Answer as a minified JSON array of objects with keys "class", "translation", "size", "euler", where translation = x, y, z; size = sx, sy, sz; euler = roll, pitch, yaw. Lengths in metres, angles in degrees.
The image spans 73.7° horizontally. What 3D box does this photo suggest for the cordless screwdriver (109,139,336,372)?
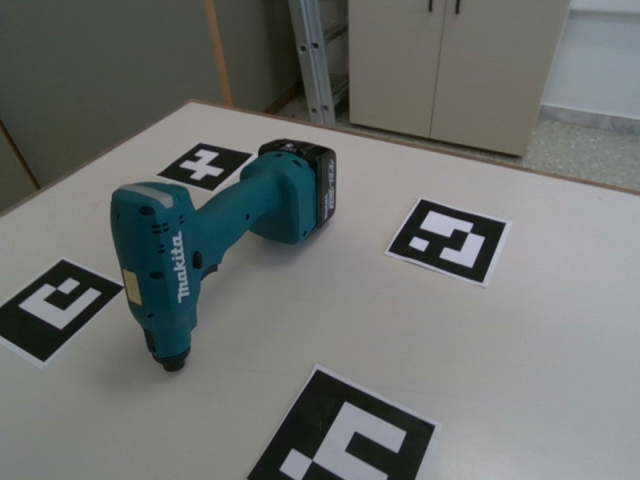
[{"class":"cordless screwdriver","translation":[-0.074,-0.002,0.403],"size":[0.075,0.159,0.246],"euler":[15,30,26]}]
